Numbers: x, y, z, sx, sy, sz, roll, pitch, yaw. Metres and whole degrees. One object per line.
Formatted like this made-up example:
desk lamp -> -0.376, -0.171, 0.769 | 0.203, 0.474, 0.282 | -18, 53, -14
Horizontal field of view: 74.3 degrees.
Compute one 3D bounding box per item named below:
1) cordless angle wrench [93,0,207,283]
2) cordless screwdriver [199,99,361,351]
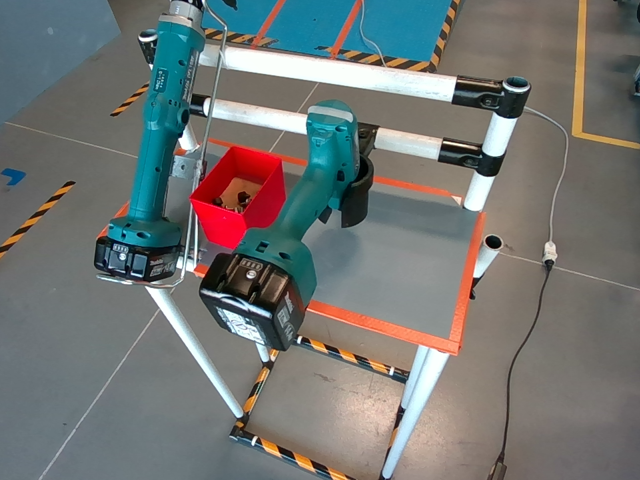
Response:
cordless angle wrench -> -0.194, -0.159, 0.538 | 0.074, 0.423, 0.098 | 15, 6, 9
cordless screwdriver -> -0.017, -0.008, 0.449 | 0.074, 0.248, 0.159 | 16, -28, 19
